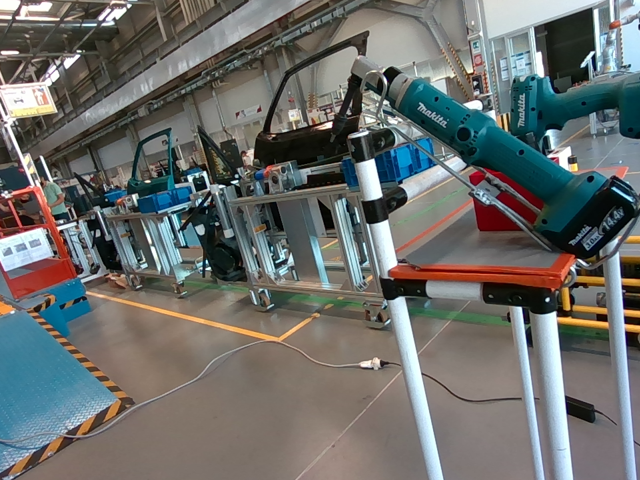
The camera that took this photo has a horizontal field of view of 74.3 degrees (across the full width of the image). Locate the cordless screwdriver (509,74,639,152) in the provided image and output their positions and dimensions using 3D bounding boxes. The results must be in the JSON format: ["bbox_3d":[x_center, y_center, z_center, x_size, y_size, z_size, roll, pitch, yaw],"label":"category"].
[{"bbox_3d":[0.432,-0.189,0.673,0.249,0.159,0.074,10,26,40],"label":"cordless screwdriver"}]

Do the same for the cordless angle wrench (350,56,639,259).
[{"bbox_3d":[0.204,-0.142,0.577,0.422,0.098,0.074,41,36,19],"label":"cordless angle wrench"}]
